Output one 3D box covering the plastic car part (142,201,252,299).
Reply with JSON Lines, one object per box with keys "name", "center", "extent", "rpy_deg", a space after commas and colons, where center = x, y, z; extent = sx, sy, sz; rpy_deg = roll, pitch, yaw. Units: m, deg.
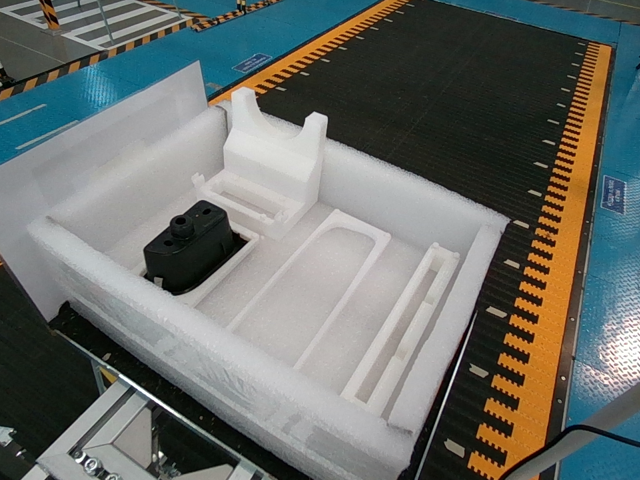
{"name": "plastic car part", "center": [-0.134, 0.003, 0.444], "extent": [0.066, 0.071, 0.116], "rpy_deg": [25, 46, 20]}
